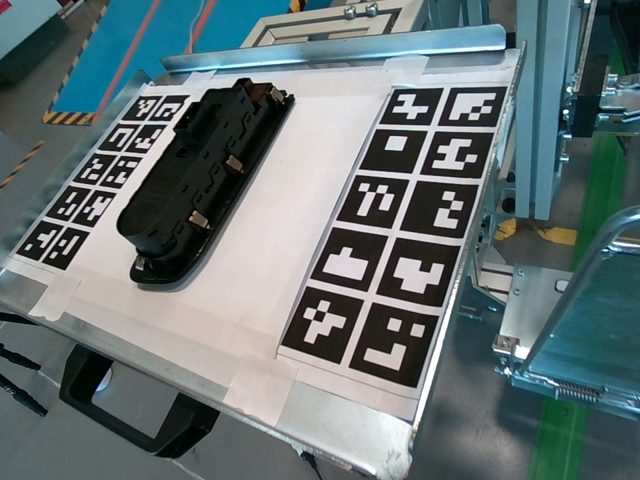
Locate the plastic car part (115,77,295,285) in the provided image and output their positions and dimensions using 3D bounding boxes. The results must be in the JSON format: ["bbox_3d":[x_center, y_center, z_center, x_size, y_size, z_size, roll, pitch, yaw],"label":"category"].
[{"bbox_3d":[-0.090,-0.058,0.332,0.067,0.202,0.067,12,-24,24],"label":"plastic car part"}]
